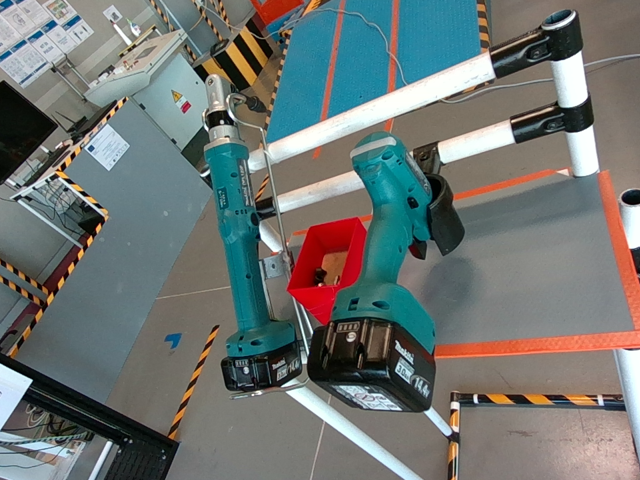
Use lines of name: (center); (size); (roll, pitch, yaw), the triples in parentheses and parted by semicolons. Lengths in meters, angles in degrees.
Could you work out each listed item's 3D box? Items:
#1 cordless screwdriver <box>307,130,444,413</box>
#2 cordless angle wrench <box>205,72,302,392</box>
cordless screwdriver: (0.075, 0.033, 0.405); (0.074, 0.248, 0.159); (-12, -38, 35)
cordless angle wrench: (-0.106, -0.020, 0.566); (0.074, 0.422, 0.098); (-12, -4, 26)
